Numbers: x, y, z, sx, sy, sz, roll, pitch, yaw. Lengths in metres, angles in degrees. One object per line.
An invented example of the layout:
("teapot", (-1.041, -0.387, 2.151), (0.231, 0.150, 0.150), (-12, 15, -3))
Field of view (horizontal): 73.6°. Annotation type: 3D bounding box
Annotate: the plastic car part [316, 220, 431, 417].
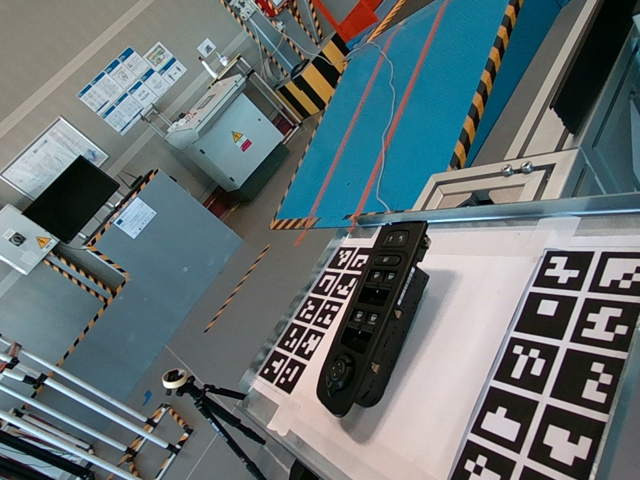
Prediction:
("plastic car part", (0.059, 0.079, 0.429), (0.067, 0.202, 0.067), (6, -30, 50))
